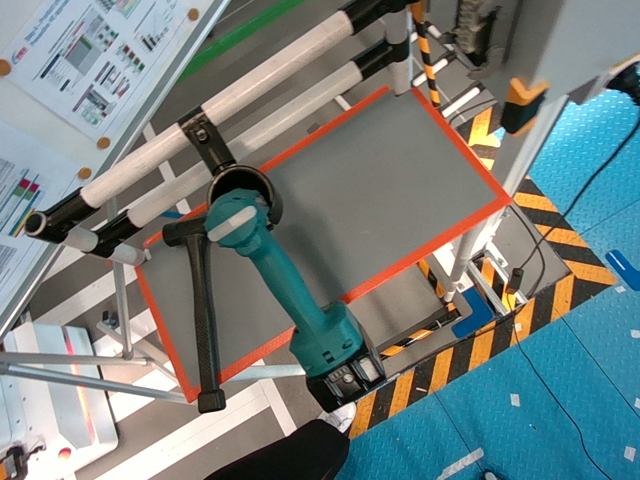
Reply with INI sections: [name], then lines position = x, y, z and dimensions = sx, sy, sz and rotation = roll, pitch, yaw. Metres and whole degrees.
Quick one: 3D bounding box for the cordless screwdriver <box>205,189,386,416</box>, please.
[cordless screwdriver]
position = -0.030, 0.054, 0.465
dimensions = 0.074, 0.249, 0.159
rotation = -32, 11, 1
